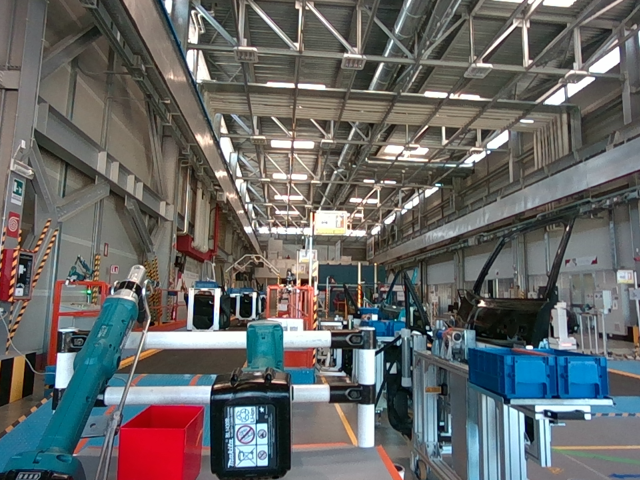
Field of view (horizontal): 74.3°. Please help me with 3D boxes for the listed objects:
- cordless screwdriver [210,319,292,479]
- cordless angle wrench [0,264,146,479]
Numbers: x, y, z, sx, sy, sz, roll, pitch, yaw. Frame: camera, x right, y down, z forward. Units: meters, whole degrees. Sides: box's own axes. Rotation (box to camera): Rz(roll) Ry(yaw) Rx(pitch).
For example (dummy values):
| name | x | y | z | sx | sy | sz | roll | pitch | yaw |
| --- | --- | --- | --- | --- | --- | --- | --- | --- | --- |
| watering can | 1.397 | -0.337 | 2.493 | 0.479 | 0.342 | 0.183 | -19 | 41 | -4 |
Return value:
| name | x | y | z | sx | sy | sz | roll | pitch | yaw |
| --- | --- | --- | --- | --- | --- | --- | --- | --- | --- |
| cordless screwdriver | -0.070 | 0.198 | 0.501 | 0.074 | 0.159 | 0.249 | -2 | 2 | -4 |
| cordless angle wrench | -0.310 | 0.171 | 0.585 | 0.074 | 0.098 | 0.421 | 7 | 35 | -9 |
